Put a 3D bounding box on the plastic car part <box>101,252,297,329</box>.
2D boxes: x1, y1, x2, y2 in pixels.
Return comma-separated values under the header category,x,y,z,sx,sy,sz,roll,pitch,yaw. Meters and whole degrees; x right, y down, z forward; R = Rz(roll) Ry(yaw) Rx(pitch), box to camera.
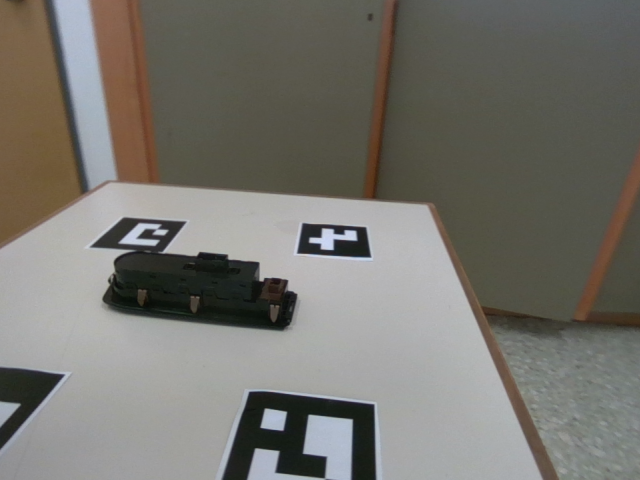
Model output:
category,x,y,z,sx,sy,sz,roll,pitch,yaw
plastic car part,-0.128,0.047,0.440,0.203,0.067,0.066,2,32,5
